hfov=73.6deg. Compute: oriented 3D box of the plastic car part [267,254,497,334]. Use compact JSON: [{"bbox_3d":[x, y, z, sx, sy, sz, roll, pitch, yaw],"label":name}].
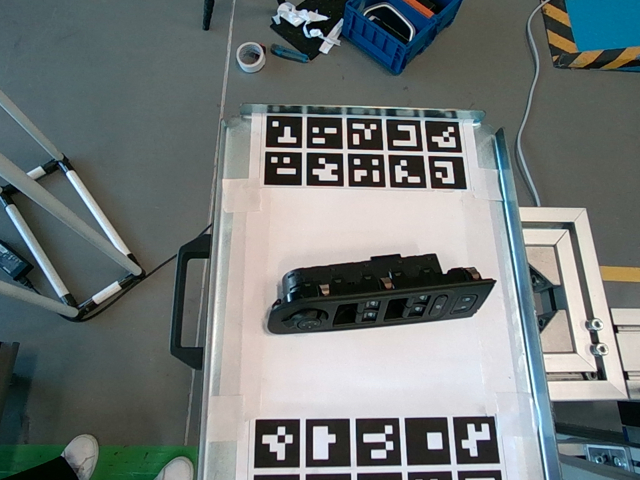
[{"bbox_3d":[0.050,0.046,0.394,0.203,0.067,0.066,-9,-29,-8],"label":"plastic car part"}]
